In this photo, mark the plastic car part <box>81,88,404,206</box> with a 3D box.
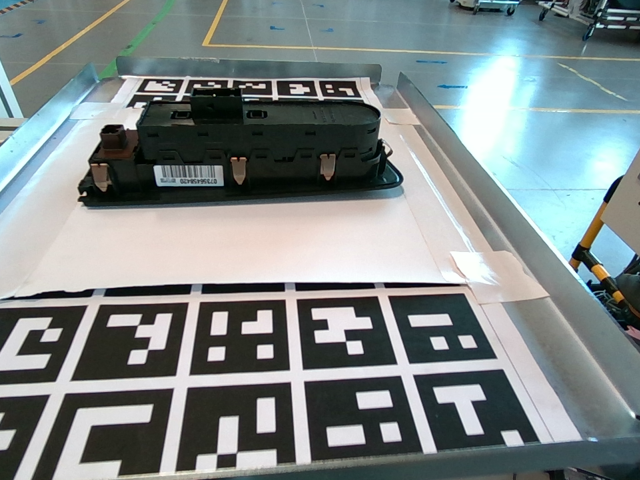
[{"bbox_3d":[-0.045,-0.064,0.277,0.203,0.067,0.066,0,32,-9],"label":"plastic car part"}]
